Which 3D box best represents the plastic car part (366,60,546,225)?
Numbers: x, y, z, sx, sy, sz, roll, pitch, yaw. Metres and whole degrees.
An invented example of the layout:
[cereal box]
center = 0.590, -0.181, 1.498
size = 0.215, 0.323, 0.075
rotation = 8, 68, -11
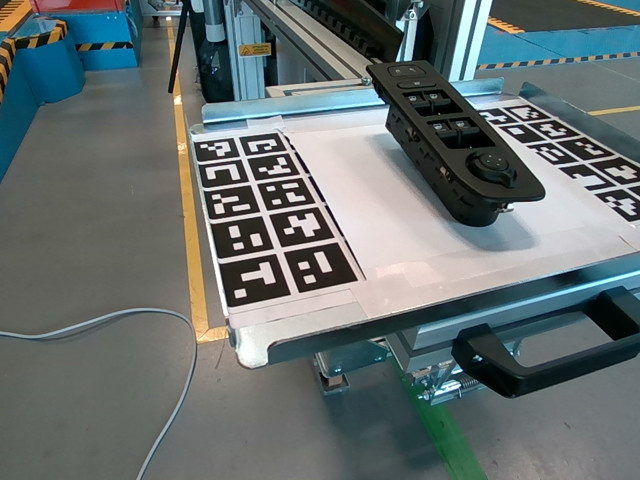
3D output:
[plastic car part]
center = 0.101, -0.085, 0.365
size = 0.066, 0.067, 0.203
rotation = -6, 44, -21
